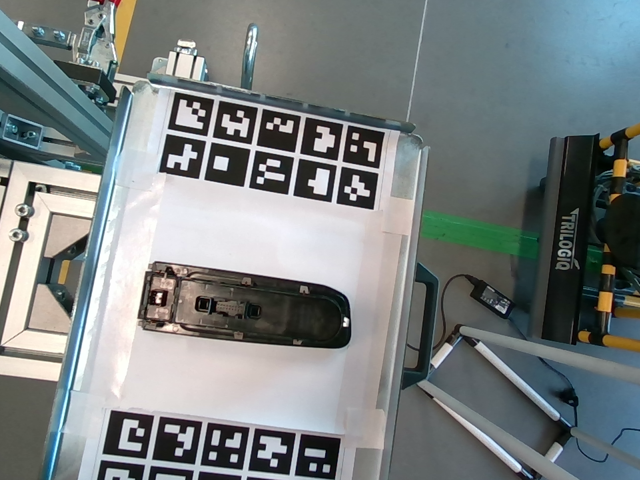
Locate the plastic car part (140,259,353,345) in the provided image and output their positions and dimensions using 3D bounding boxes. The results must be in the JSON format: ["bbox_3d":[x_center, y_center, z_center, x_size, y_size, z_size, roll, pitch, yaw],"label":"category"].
[{"bbox_3d":[-0.063,0.060,0.393,0.203,0.066,0.067,8,-13,-8],"label":"plastic car part"}]
